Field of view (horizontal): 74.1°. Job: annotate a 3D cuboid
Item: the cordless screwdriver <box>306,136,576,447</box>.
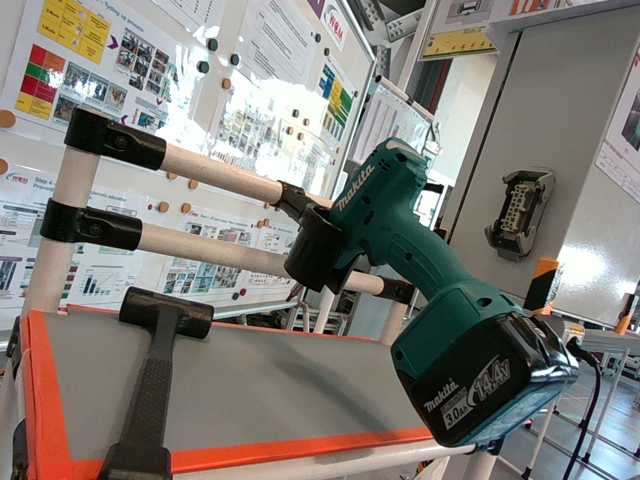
[{"bbox_3d":[0.067,0.042,0.357,0.074,0.249,0.160,12,-52,-38],"label":"cordless screwdriver"}]
